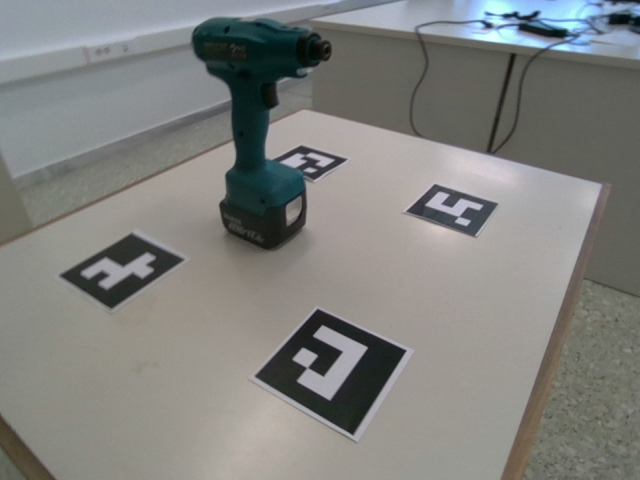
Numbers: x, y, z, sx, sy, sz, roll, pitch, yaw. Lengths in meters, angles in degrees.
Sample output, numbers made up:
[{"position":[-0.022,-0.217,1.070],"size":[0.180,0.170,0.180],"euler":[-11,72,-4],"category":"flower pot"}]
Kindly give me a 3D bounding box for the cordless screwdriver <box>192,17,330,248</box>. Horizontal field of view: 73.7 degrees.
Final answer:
[{"position":[-0.055,-0.110,0.480],"size":[0.161,0.248,0.074],"euler":[20,39,31],"category":"cordless screwdriver"}]
